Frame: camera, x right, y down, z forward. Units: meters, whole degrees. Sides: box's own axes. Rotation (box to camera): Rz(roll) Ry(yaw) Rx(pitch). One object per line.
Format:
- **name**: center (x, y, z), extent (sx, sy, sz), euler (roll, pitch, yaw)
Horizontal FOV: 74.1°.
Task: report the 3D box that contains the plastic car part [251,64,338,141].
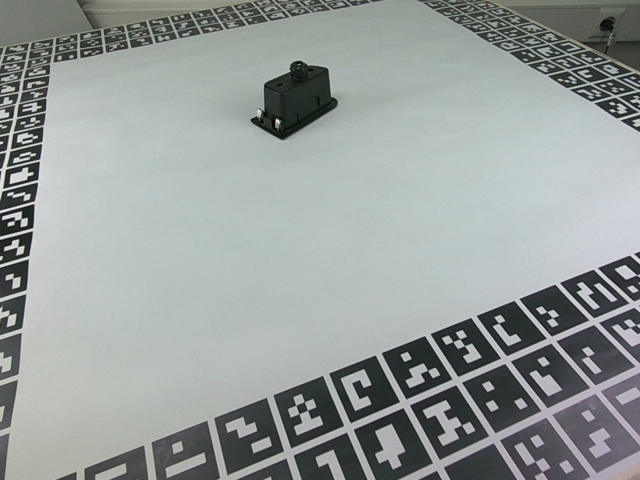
- **plastic car part**: center (-0.031, -0.192, 0.559), extent (0.116, 0.071, 0.066), euler (-38, 56, -25)
